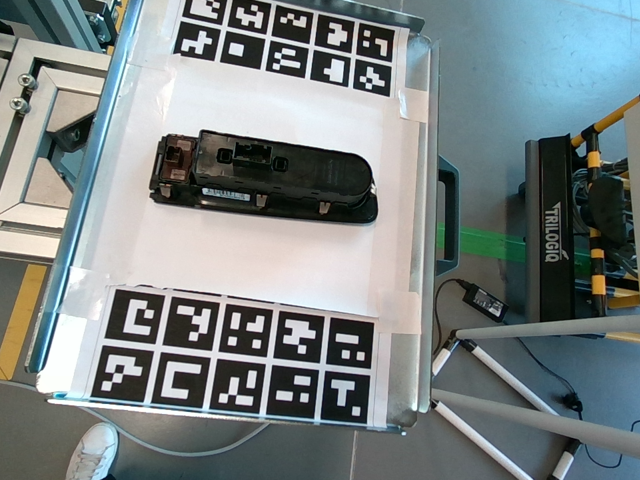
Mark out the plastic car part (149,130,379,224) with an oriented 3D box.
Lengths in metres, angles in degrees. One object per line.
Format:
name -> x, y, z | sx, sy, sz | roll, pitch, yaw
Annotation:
plastic car part -> -0.040, -0.059, 0.369 | 0.203, 0.066, 0.067 | 8, -22, -11
